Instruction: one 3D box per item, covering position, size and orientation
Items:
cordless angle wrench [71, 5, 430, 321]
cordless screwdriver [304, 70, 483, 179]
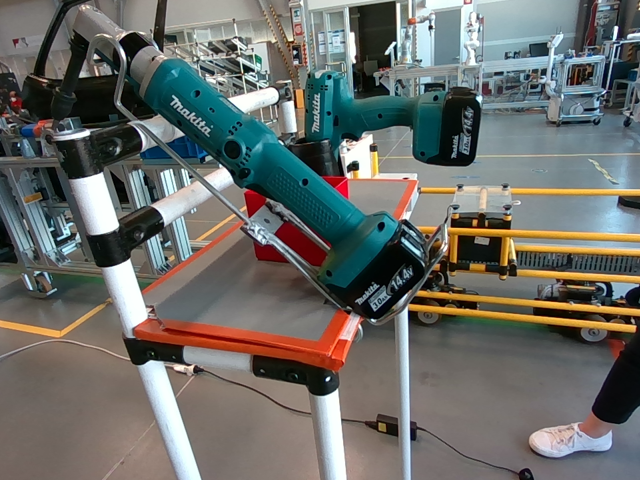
[{"bbox_3d":[-0.077,-0.090,0.423,0.423,0.098,0.074,40,24,-1],"label":"cordless angle wrench"},{"bbox_3d":[0.094,-0.148,0.601,0.249,0.159,0.074,12,28,17],"label":"cordless screwdriver"}]
